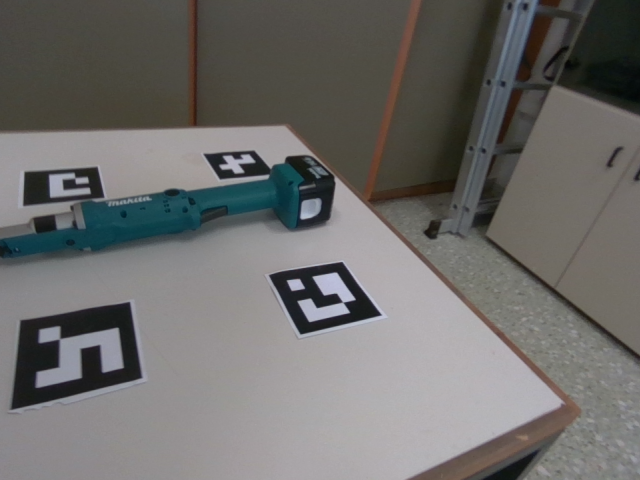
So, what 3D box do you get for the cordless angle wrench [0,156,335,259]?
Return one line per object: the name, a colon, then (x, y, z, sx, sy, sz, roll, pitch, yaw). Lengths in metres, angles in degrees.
cordless angle wrench: (-0.183, -0.035, 0.543, 0.419, 0.074, 0.098, -13, 41, -25)
